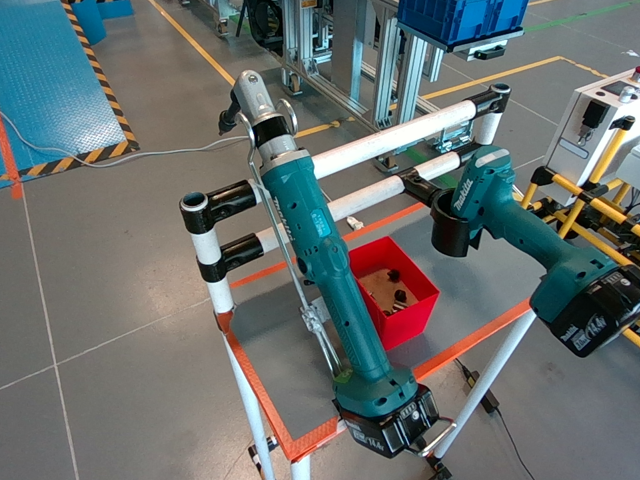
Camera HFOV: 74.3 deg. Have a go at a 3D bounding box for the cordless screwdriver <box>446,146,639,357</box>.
[{"bbox_3d":[0.248,0.019,0.512,0.074,0.248,0.160,-23,-32,-19],"label":"cordless screwdriver"}]

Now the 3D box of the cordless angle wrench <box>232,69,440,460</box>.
[{"bbox_3d":[0.001,0.019,0.453,0.074,0.423,0.098,-24,3,-30],"label":"cordless angle wrench"}]
